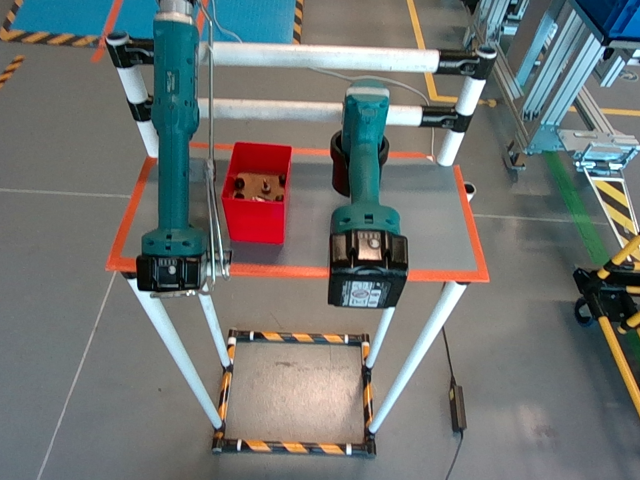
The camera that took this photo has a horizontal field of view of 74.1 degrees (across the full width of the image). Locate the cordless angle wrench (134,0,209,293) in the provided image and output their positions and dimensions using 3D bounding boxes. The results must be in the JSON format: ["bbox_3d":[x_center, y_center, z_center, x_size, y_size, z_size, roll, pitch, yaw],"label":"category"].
[{"bbox_3d":[-0.176,-0.150,0.517,0.074,0.422,0.098,1,4,-7],"label":"cordless angle wrench"}]

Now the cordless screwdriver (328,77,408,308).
[{"bbox_3d":[0.049,-0.043,0.492,0.074,0.248,0.159,2,-28,1],"label":"cordless screwdriver"}]
